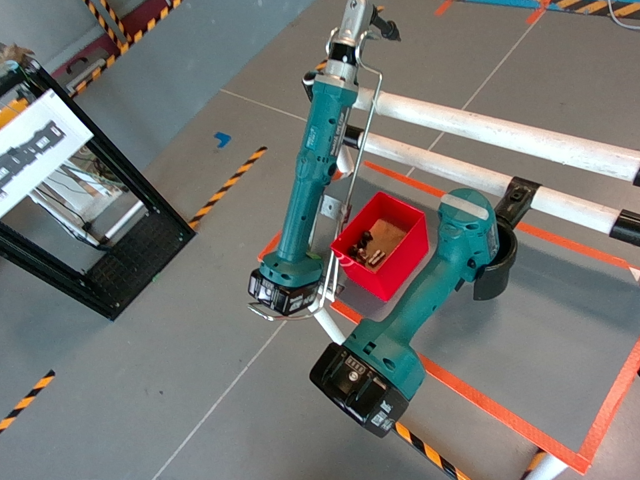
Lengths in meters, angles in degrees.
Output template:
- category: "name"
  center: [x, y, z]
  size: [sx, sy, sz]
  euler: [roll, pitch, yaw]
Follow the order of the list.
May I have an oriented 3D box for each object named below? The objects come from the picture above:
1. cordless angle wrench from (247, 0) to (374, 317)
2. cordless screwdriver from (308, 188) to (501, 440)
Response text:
- category: "cordless angle wrench"
  center: [-0.004, -0.101, 0.573]
  size: [0.074, 0.423, 0.098]
  euler: [25, 19, 28]
- category: "cordless screwdriver"
  center: [0.107, 0.081, 0.444]
  size: [0.074, 0.248, 0.159]
  euler: [31, -10, 36]
